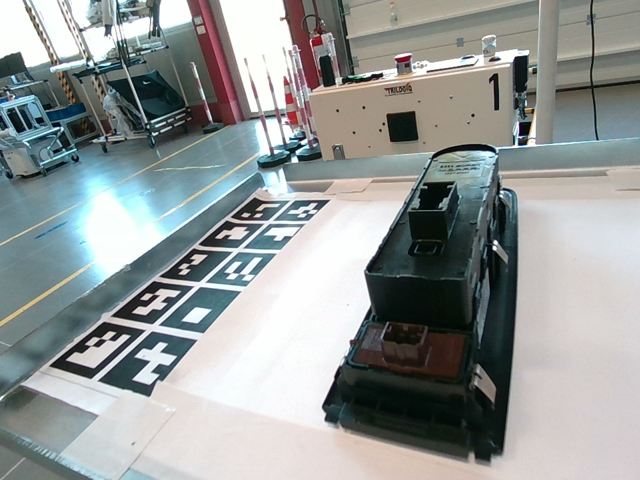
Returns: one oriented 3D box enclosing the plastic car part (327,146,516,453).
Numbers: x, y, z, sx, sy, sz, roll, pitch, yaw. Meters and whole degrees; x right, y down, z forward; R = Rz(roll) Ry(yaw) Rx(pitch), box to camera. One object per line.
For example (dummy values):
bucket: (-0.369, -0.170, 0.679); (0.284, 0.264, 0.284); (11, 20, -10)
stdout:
plastic car part: (0.064, 0.001, 0.226); (0.067, 0.067, 0.201); (-6, 25, 32)
